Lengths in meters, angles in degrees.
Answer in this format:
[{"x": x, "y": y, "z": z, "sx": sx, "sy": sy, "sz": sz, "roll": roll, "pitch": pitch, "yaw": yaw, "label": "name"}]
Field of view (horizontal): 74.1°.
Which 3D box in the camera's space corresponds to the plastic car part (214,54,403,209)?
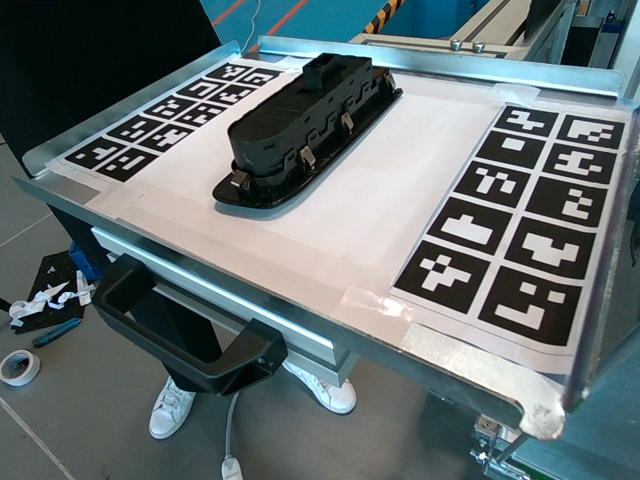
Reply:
[{"x": -0.003, "y": -0.096, "z": 0.324, "sx": 0.066, "sy": 0.202, "sz": 0.067, "roll": 23, "pitch": -36, "yaw": 21, "label": "plastic car part"}]
